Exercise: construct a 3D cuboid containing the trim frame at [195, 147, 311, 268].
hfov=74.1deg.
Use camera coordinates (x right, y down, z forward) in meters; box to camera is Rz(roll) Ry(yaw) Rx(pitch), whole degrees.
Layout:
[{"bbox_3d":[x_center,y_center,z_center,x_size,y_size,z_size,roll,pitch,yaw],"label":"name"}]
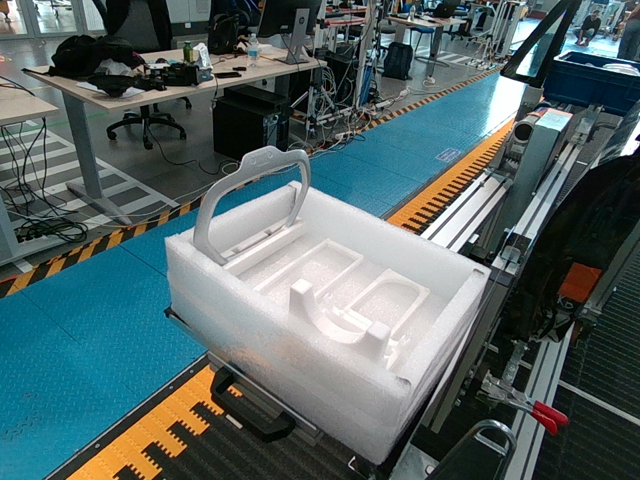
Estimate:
[{"bbox_3d":[-0.096,-0.053,0.661,0.027,0.184,0.247,34,45,26],"label":"trim frame"}]
